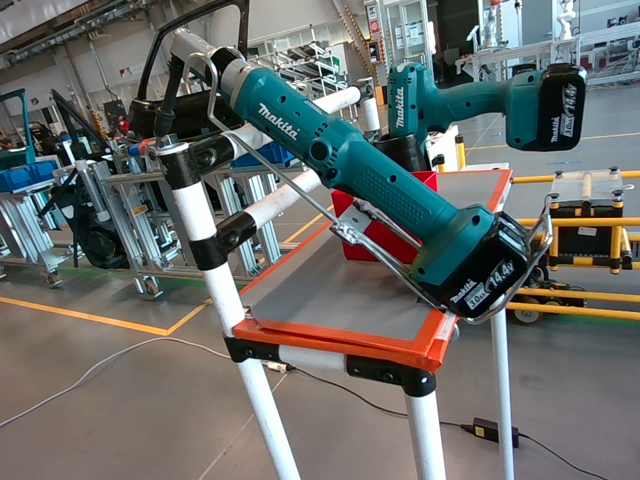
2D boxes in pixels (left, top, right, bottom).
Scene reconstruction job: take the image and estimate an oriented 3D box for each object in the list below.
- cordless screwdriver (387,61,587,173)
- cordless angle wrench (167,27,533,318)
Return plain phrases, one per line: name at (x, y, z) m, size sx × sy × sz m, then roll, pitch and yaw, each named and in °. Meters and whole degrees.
cordless screwdriver at (0.211, -0.159, 0.574) m, size 0.249 × 0.159 × 0.074 m, roll 10°, pitch 32°, yaw 27°
cordless angle wrench at (0.010, -0.091, 0.427) m, size 0.423 × 0.098 × 0.074 m, roll 38°, pitch 33°, yaw 7°
